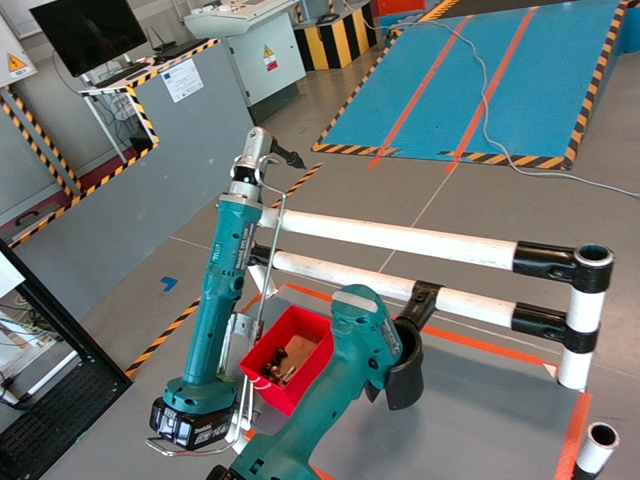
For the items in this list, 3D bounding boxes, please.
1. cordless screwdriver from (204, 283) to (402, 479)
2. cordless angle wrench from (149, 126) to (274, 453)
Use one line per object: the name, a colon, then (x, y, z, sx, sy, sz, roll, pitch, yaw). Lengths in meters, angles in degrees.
cordless screwdriver: (0.006, 0.178, 0.399, 0.074, 0.248, 0.159, 12, -36, 38)
cordless angle wrench: (-0.126, 0.054, 0.566, 0.074, 0.422, 0.098, 12, -2, 31)
